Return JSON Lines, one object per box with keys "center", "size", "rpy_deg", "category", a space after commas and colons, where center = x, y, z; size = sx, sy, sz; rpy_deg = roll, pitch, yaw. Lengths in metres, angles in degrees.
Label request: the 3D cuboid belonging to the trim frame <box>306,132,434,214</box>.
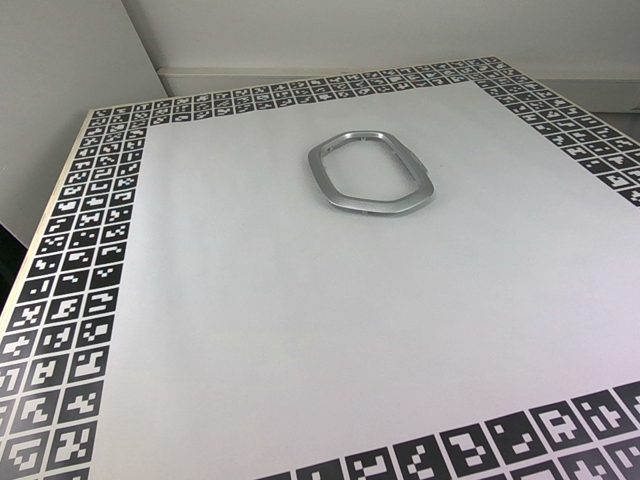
{"center": [0.077, -0.115, 0.687], "size": [0.184, 0.027, 0.248], "rpy_deg": [-14, 41, -8], "category": "trim frame"}
